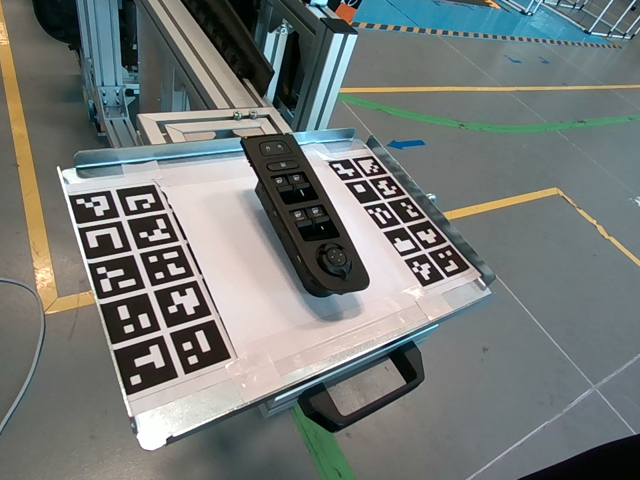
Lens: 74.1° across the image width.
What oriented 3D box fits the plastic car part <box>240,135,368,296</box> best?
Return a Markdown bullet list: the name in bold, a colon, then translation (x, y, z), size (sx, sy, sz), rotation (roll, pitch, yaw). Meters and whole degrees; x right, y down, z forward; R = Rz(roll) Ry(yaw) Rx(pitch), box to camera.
- **plastic car part**: translation (-0.025, -0.022, 0.451), size (0.066, 0.203, 0.067), rotation (-10, -33, -38)
